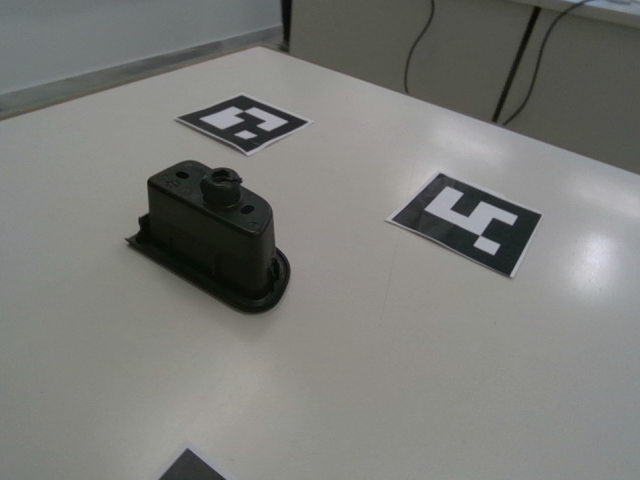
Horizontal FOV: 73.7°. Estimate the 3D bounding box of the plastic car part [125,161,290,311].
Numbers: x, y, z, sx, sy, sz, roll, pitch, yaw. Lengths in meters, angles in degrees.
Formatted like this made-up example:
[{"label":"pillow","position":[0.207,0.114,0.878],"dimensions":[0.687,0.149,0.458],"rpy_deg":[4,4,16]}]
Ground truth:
[{"label":"plastic car part","position":[-0.068,-0.014,0.277],"dimensions":[0.117,0.071,0.065],"rpy_deg":[25,44,25]}]
